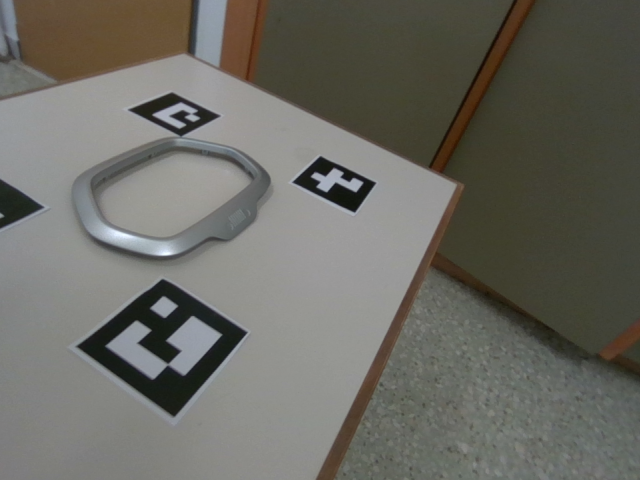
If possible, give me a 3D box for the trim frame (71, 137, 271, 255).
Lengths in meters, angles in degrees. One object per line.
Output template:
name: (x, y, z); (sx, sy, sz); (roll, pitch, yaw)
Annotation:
trim frame: (-0.164, -0.062, 0.505); (0.185, 0.027, 0.247); (25, 38, 12)
